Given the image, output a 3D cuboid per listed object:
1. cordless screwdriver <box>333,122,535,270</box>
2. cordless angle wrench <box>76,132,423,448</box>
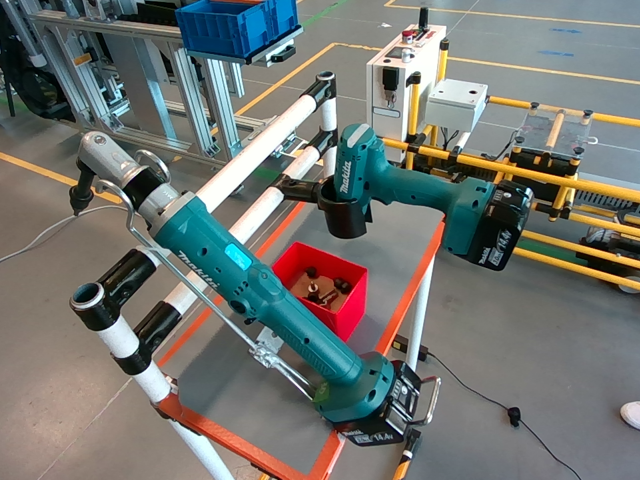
[{"bbox_3d":[0.130,-0.042,0.555,0.249,0.074,0.159,26,-36,16],"label":"cordless screwdriver"},{"bbox_3d":[-0.070,0.050,0.429,0.098,0.423,0.074,-36,14,45],"label":"cordless angle wrench"}]
